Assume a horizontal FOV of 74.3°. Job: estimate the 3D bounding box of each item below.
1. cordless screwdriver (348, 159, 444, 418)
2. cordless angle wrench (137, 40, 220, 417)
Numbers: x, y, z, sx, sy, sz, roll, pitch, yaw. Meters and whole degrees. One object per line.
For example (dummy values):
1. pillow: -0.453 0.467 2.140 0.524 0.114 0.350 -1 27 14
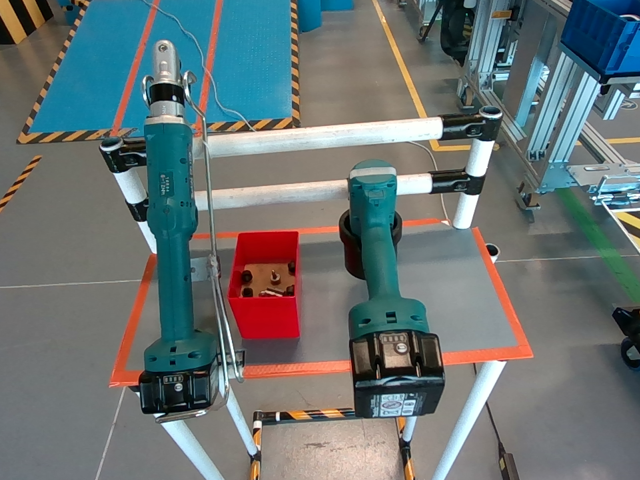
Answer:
1. cordless screwdriver: 0.064 0.055 0.448 0.074 0.248 0.159 -4 -36 3
2. cordless angle wrench: -0.168 -0.024 0.488 0.074 0.422 0.098 -4 -4 -6
